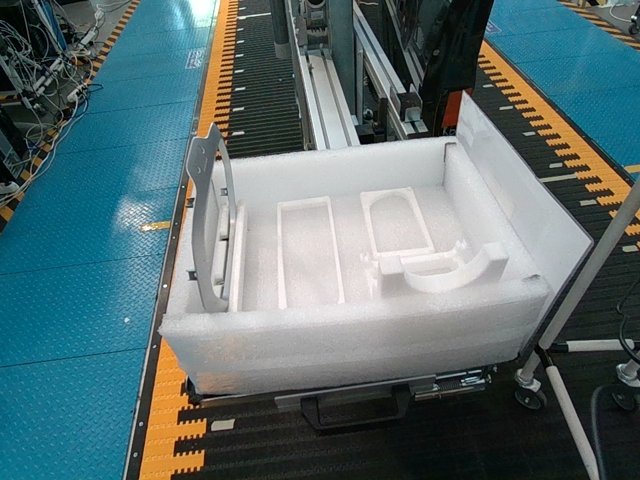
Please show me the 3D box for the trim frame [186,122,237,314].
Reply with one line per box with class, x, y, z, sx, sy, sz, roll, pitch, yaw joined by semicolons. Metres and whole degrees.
trim frame;-0.125;-0.028;0.502;0.027;0.248;0.184;-1;-41;-1
